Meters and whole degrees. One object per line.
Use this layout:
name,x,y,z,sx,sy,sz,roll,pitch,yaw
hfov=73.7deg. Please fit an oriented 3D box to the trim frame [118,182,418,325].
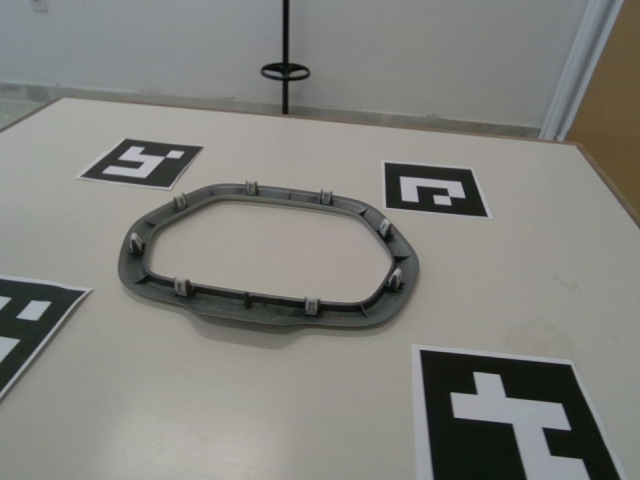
trim frame,-0.043,0.002,0.360,0.249,0.027,0.183,9,39,6
